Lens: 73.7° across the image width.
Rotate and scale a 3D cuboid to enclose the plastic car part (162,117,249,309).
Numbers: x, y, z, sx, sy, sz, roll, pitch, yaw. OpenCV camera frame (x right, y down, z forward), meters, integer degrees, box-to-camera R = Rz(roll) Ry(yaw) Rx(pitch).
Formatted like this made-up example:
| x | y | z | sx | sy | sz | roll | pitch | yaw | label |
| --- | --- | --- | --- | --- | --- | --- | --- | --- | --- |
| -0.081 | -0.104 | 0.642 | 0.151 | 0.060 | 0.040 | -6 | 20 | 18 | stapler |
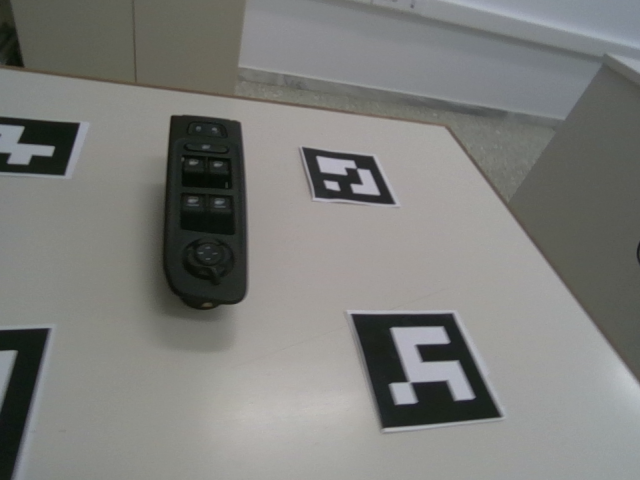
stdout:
| x | y | z | sx | sy | sz | roll | pitch | yaw | label |
| --- | --- | --- | --- | --- | --- | --- | --- | --- | --- |
| -0.099 | -0.024 | 0.365 | 0.066 | 0.203 | 0.067 | 6 | -45 | -22 | plastic car part |
